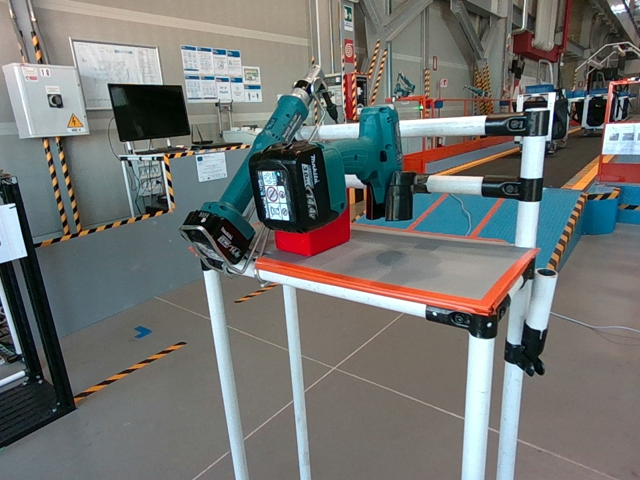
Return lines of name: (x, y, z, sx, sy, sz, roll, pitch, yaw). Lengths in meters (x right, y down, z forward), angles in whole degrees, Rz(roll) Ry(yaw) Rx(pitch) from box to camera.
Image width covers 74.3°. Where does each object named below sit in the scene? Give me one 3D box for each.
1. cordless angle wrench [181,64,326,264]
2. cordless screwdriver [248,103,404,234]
cordless angle wrench: (-0.089, -0.159, 0.744, 0.074, 0.422, 0.098, 13, -25, 31)
cordless screwdriver: (0.032, -0.072, 0.536, 0.074, 0.159, 0.248, 8, 28, 40)
